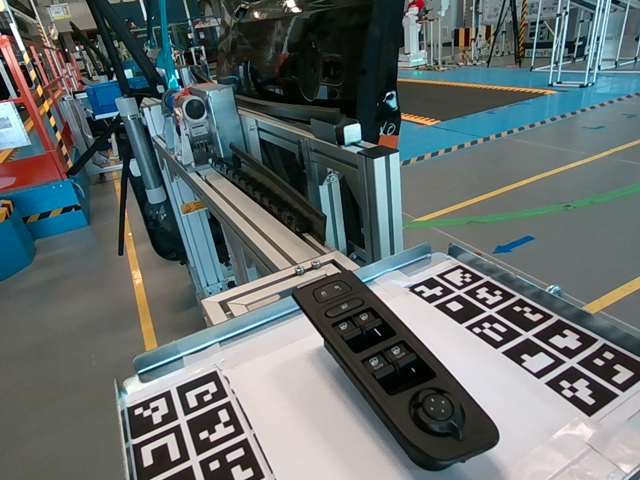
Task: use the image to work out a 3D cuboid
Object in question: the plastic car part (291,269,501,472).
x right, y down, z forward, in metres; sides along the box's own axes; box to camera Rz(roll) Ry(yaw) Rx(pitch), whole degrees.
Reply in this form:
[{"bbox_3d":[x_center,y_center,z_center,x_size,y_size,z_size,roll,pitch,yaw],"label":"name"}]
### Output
[{"bbox_3d":[0.048,0.104,0.348,0.066,0.067,0.203,-14,31,-26],"label":"plastic car part"}]
